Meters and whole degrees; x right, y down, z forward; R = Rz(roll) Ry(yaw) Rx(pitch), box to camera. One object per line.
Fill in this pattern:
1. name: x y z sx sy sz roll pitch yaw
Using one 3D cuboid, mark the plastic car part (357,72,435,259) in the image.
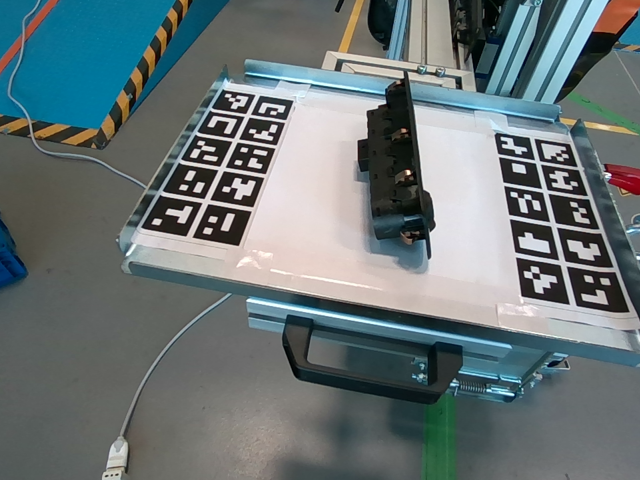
1. plastic car part: 0.068 -0.073 0.394 0.067 0.202 0.066 -5 -40 4
